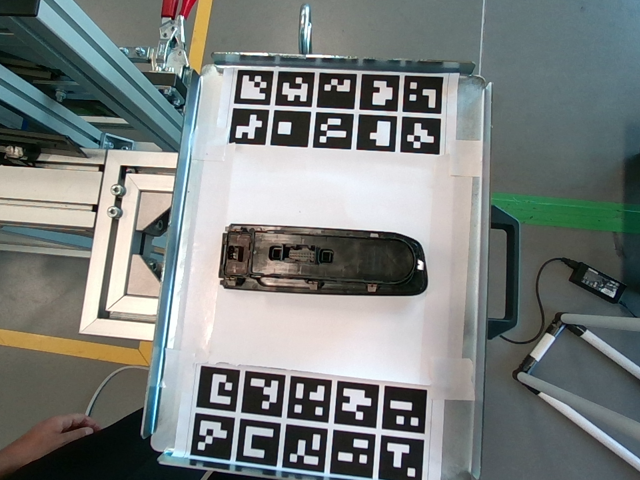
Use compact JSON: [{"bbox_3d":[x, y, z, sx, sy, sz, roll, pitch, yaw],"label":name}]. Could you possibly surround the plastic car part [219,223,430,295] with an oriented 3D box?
[{"bbox_3d":[0.003,0.015,0.399,0.203,0.066,0.067,4,-14,3],"label":"plastic car part"}]
